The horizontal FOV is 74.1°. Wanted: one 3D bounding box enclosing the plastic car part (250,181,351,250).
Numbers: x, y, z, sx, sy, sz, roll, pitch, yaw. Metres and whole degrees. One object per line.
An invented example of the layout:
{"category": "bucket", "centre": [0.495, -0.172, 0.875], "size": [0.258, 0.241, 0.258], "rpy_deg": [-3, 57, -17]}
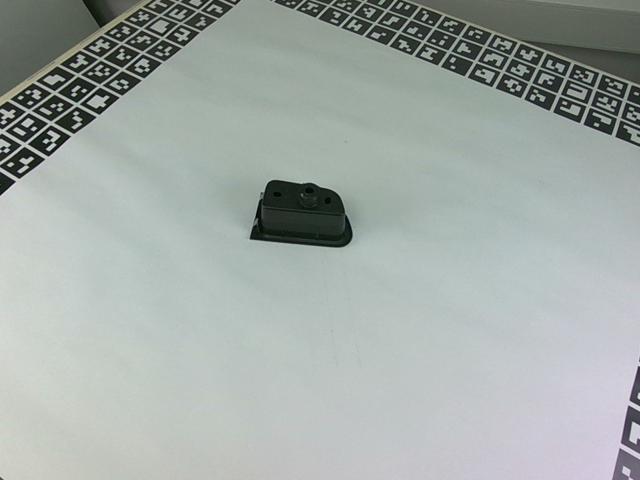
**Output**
{"category": "plastic car part", "centre": [-0.020, -0.034, 0.482], "size": [0.117, 0.066, 0.071], "rpy_deg": [7, -32, 7]}
